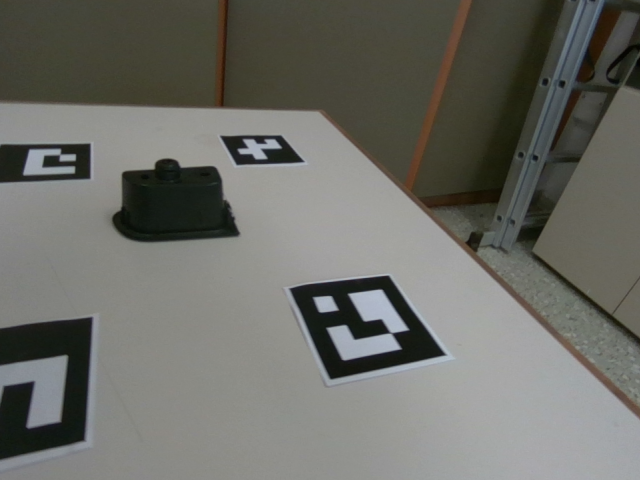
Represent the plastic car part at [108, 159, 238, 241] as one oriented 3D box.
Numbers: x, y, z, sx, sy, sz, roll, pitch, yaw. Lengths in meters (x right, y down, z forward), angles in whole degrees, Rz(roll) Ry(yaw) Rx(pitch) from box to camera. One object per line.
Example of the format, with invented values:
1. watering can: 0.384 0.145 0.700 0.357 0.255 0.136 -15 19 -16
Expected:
1. plastic car part: -0.142 -0.043 0.415 0.115 0.071 0.066 -3 33 -29
